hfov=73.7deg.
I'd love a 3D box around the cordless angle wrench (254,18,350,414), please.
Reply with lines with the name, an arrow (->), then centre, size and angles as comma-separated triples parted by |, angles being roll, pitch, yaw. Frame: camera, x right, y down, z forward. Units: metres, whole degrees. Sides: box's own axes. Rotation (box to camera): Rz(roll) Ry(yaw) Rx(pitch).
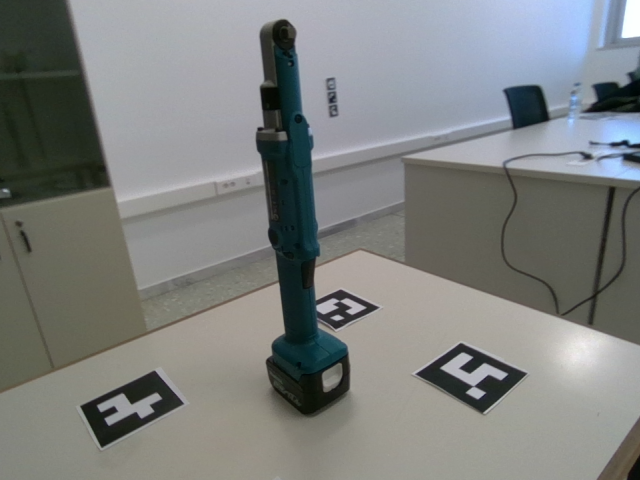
cordless angle wrench -> -0.030, -0.009, 0.474 | 0.073, 0.422, 0.099 | -20, 25, -36
